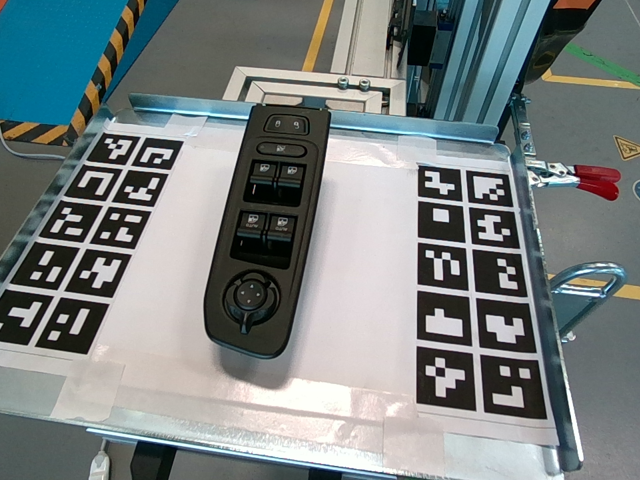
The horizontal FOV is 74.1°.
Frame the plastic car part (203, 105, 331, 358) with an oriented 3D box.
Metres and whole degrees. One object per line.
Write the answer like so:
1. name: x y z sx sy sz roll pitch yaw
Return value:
1. plastic car part: -0.039 -0.010 0.321 0.066 0.202 0.067 10 -31 -3
